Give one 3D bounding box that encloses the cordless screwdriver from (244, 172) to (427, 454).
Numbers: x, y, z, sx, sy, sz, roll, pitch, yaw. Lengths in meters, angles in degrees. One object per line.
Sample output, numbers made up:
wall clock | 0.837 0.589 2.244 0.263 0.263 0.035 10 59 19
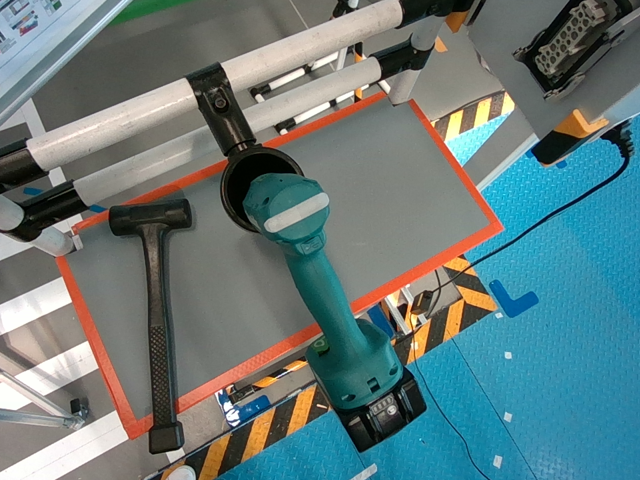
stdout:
cordless screwdriver | 0.001 0.054 0.390 0.074 0.249 0.159 -27 17 -11
